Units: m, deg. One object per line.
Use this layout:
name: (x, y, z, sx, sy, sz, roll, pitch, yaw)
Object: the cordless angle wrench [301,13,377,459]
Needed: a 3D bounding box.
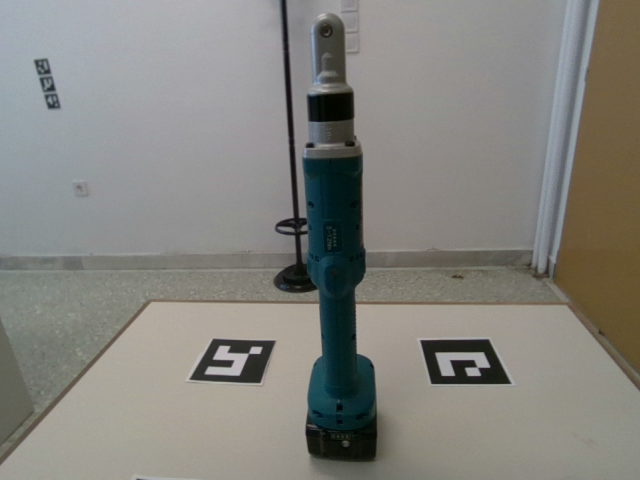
cordless angle wrench: (0.016, 0.020, 0.408, 0.074, 0.422, 0.098, -1, 21, 7)
